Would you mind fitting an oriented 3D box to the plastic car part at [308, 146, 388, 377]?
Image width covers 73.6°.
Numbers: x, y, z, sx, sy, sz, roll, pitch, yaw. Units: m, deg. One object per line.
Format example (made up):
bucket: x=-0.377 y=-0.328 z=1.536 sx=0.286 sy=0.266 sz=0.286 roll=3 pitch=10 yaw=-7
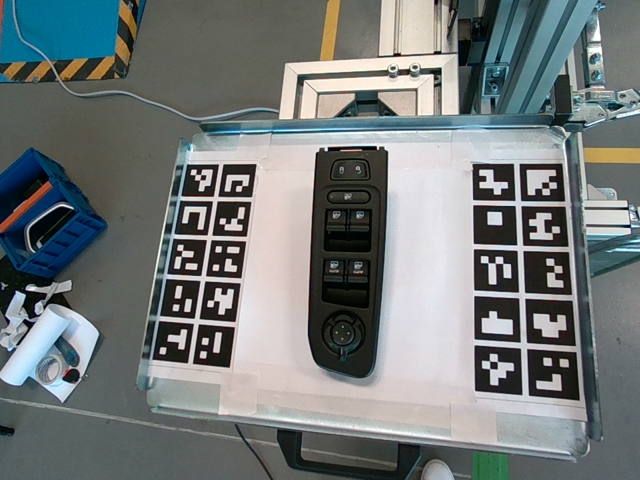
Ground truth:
plastic car part: x=0.025 y=0.019 z=0.396 sx=0.066 sy=0.202 sz=0.067 roll=3 pitch=-12 yaw=3
